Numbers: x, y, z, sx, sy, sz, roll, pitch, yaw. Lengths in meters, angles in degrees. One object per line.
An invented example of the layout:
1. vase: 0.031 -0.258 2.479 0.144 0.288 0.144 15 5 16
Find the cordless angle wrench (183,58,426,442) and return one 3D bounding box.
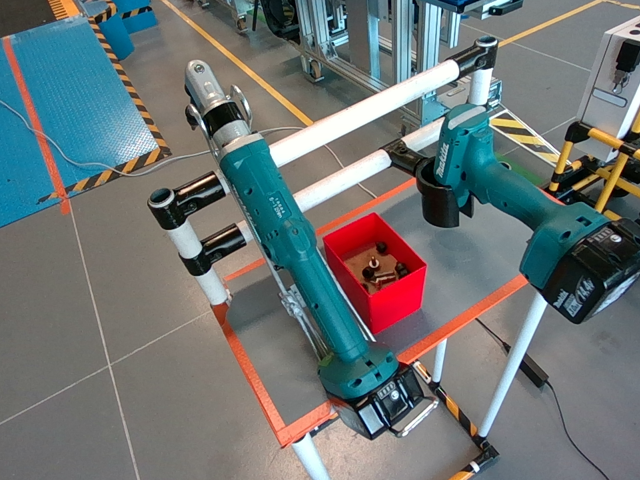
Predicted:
1. cordless angle wrench: -0.033 0.001 0.444 0.074 0.423 0.098 -29 2 -21

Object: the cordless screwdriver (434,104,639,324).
1. cordless screwdriver: 0.217 -0.023 0.473 0.074 0.248 0.159 -28 -32 -12
